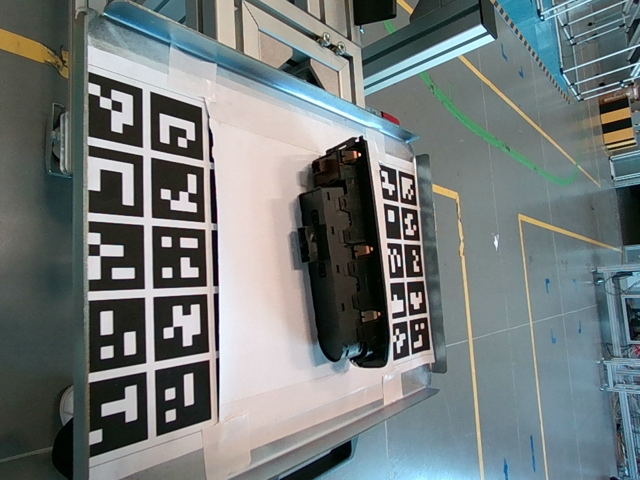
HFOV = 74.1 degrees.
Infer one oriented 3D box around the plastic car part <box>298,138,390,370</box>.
[{"bbox_3d":[0.018,0.020,0.365,0.066,0.203,0.067,-13,3,-38],"label":"plastic car part"}]
